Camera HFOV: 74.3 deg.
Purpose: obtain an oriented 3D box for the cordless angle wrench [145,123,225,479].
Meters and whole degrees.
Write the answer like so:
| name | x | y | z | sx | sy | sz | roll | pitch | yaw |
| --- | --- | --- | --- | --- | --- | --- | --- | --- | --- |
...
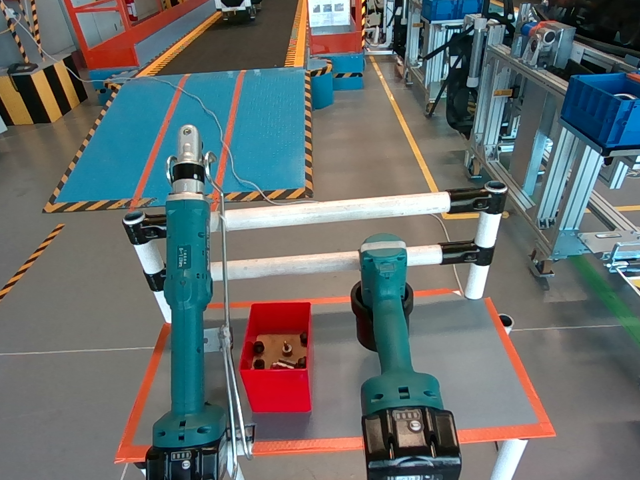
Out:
| name | x | y | z | sx | sy | sz | roll | pitch | yaw |
| --- | --- | --- | --- | --- | --- | --- | --- | --- | --- |
| cordless angle wrench | -0.157 | 0.059 | 0.502 | 0.074 | 0.422 | 0.098 | -2 | -11 | -9 |

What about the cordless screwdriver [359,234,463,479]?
| name | x | y | z | sx | sy | sz | roll | pitch | yaw |
| --- | --- | --- | --- | --- | --- | --- | --- | --- | --- |
| cordless screwdriver | 0.076 | 0.131 | 0.436 | 0.074 | 0.159 | 0.248 | -5 | 43 | 5 |
